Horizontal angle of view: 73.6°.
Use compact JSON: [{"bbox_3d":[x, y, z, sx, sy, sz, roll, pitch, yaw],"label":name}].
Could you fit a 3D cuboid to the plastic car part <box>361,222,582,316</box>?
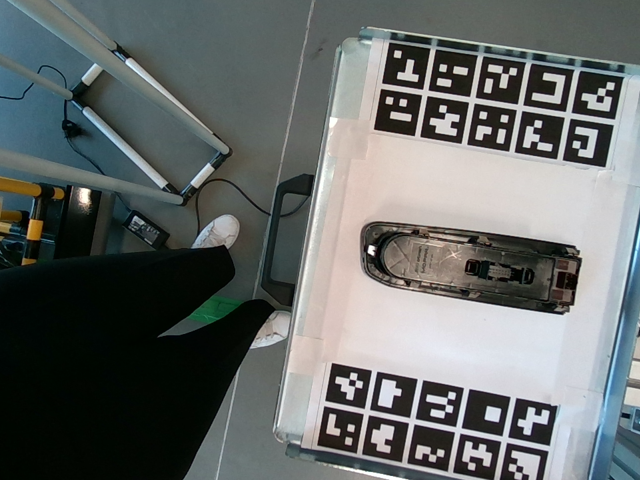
[{"bbox_3d":[0.135,0.026,0.382,0.203,0.066,0.067,9,7,5],"label":"plastic car part"}]
